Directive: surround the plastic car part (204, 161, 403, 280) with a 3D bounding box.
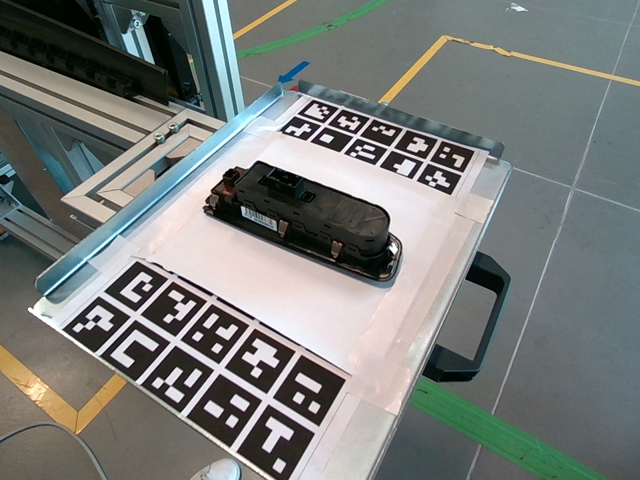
[{"bbox_3d":[-0.014,-0.030,0.402,0.203,0.067,0.066,25,48,16],"label":"plastic car part"}]
